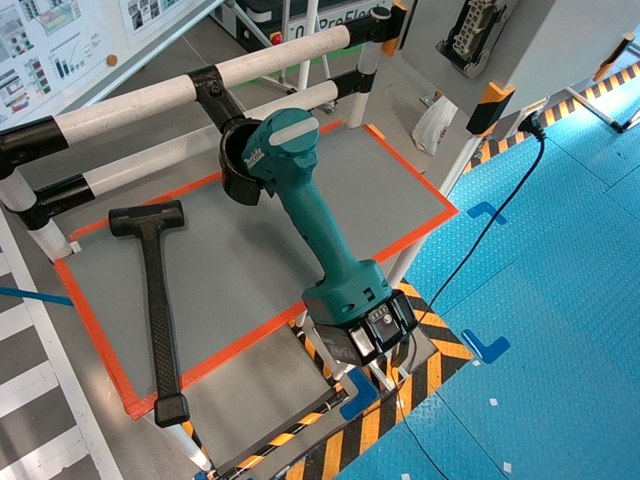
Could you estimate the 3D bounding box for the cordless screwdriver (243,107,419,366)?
[{"bbox_3d":[-0.007,0.001,0.441,0.074,0.249,0.159,-29,7,-22],"label":"cordless screwdriver"}]
